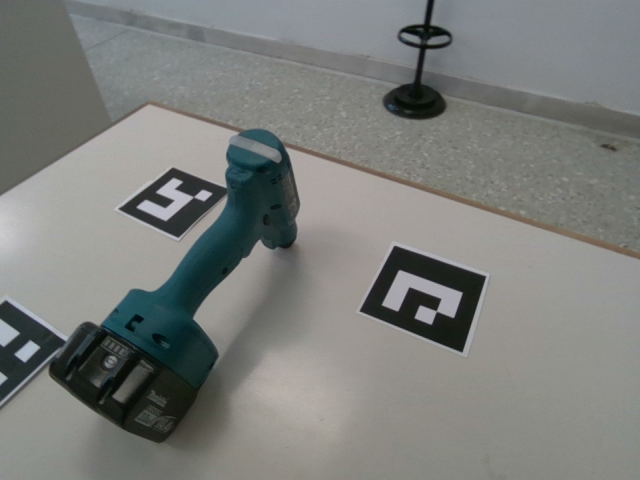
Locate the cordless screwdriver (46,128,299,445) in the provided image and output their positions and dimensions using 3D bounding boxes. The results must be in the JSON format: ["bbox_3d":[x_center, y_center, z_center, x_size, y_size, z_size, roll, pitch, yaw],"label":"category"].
[{"bbox_3d":[-0.094,0.040,0.372,0.075,0.248,0.159,24,-23,17],"label":"cordless screwdriver"}]
